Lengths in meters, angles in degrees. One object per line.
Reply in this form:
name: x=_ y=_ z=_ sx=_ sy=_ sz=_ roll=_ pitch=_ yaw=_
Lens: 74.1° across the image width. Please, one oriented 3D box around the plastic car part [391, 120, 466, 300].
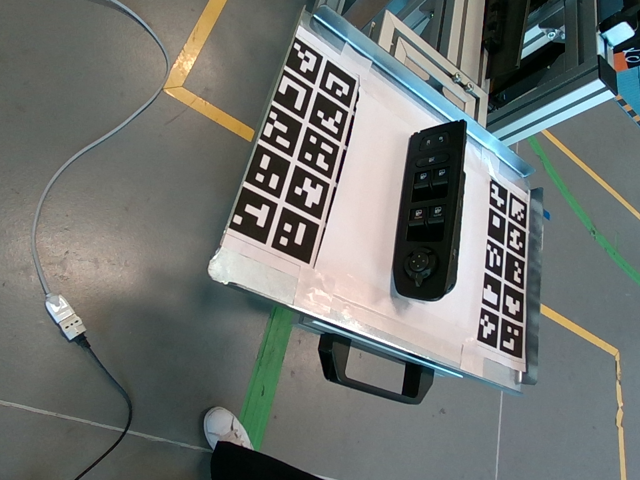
plastic car part: x=0.120 y=-0.026 z=0.456 sx=0.067 sy=0.202 sz=0.067 roll=-1 pitch=-29 yaw=32
